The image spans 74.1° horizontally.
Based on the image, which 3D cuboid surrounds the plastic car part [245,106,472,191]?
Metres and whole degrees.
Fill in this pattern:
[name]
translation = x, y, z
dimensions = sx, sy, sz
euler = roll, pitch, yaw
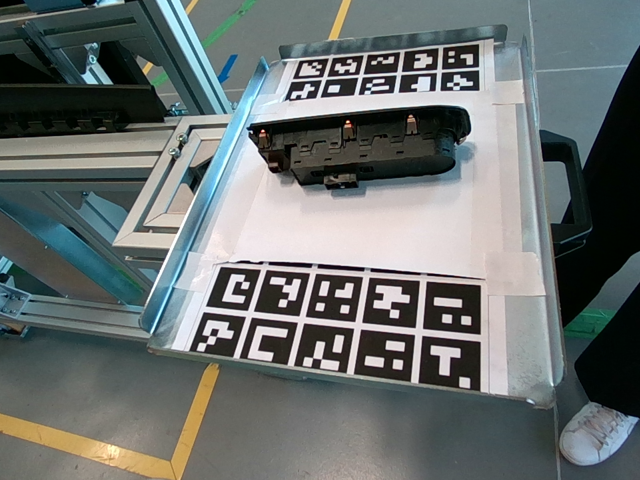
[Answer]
[plastic car part]
translation = 0.037, -0.082, 0.386
dimensions = 0.203, 0.067, 0.066
euler = -7, -24, 9
